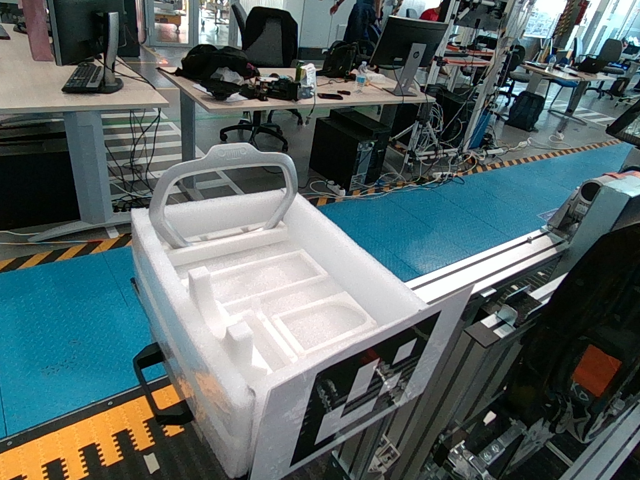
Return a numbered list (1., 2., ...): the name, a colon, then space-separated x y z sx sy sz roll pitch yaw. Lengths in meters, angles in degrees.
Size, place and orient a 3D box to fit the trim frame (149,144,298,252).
1. trim frame: -0.142 -0.063 0.668 0.247 0.185 0.027 -14 46 -30
